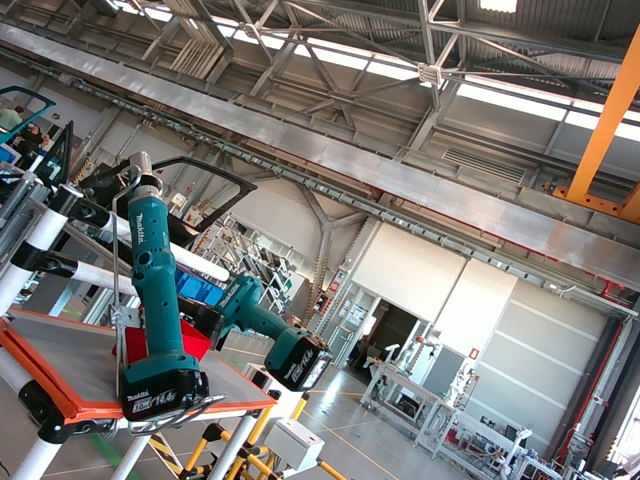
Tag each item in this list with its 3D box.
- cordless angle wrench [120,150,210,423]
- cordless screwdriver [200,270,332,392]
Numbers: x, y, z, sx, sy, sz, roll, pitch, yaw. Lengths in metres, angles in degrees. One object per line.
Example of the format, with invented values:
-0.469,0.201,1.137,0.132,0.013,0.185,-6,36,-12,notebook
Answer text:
-0.247,0.039,0.624,0.098,0.422,0.074,-19,-24,5,cordless angle wrench
-0.110,0.184,0.778,0.248,0.159,0.074,36,-5,28,cordless screwdriver
